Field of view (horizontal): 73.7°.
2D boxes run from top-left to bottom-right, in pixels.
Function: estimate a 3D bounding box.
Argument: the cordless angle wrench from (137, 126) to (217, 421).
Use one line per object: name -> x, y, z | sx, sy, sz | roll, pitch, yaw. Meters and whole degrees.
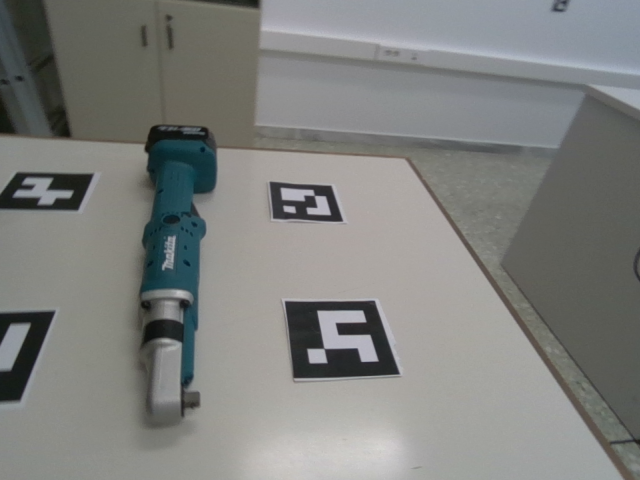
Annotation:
cordless angle wrench -> -0.162, -0.002, 0.477 | 0.097, 0.074, 0.424 | -2, 40, -13
